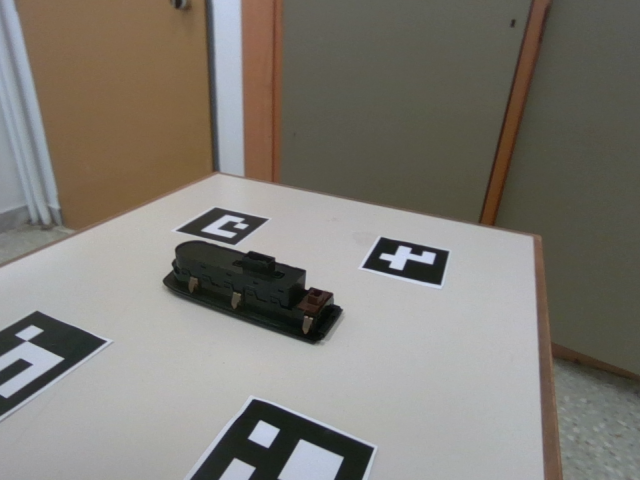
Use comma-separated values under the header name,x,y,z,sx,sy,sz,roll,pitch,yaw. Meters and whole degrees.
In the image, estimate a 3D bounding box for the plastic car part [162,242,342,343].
name,x,y,z,sx,sy,sz,roll,pitch,yaw
plastic car part,-0.081,0.045,0.448,0.204,0.067,0.066,10,32,22
